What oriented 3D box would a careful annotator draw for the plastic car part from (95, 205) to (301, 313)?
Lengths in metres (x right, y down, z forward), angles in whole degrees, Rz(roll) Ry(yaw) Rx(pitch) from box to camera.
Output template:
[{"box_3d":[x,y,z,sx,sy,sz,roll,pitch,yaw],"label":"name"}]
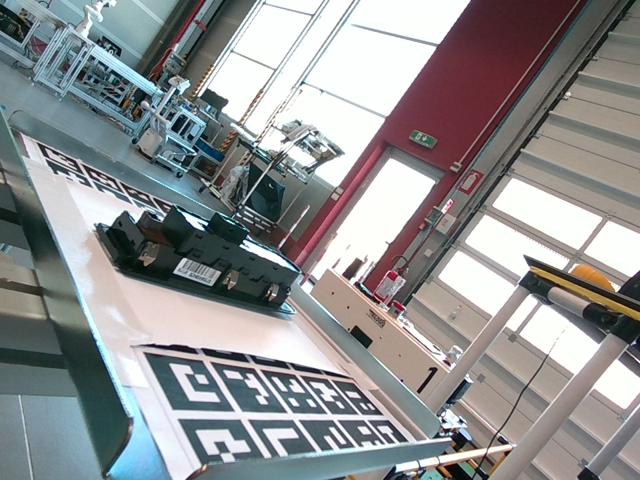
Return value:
[{"box_3d":[-0.083,0.017,0.377,0.066,0.067,0.202,31,-2,39],"label":"plastic car part"}]
